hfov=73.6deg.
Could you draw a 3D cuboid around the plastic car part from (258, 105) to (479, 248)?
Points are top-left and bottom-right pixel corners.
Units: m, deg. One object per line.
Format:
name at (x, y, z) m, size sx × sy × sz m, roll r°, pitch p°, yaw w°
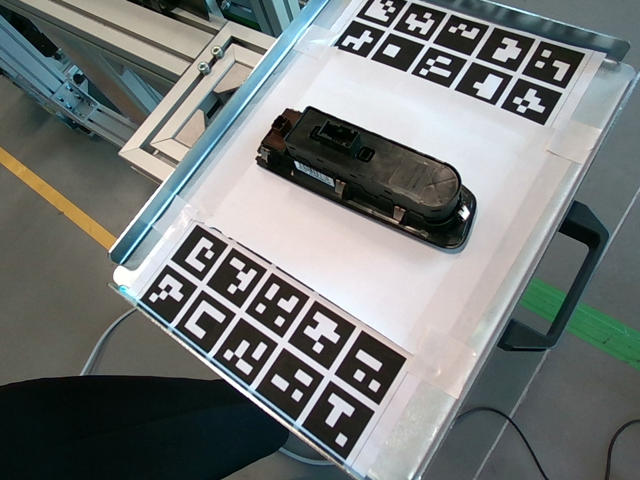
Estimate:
plastic car part at (0.037, -0.065, 0.355) m, size 0.203 × 0.066 × 0.067 m, roll 29°, pitch -19°, yaw 17°
